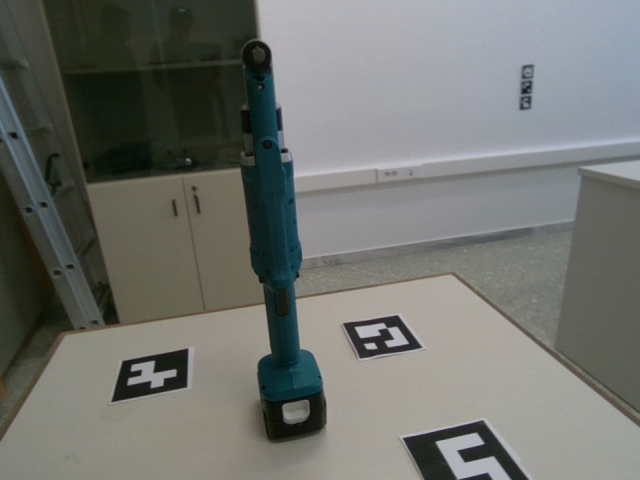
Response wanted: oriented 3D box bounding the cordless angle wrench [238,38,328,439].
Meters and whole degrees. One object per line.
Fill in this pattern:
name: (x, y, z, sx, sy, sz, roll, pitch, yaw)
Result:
cordless angle wrench: (-0.048, 0.017, 0.458, 0.074, 0.422, 0.098, -8, 21, -11)
